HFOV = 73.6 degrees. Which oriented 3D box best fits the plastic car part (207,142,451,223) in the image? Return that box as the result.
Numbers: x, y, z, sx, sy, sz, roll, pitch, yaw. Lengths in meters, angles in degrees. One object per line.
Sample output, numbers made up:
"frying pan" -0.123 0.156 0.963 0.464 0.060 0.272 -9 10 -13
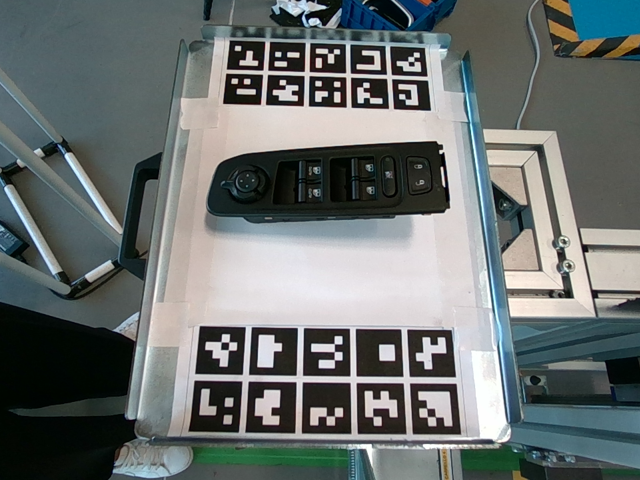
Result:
"plastic car part" 0.004 -0.045 0.379 0.203 0.066 0.067 -1 -12 2
